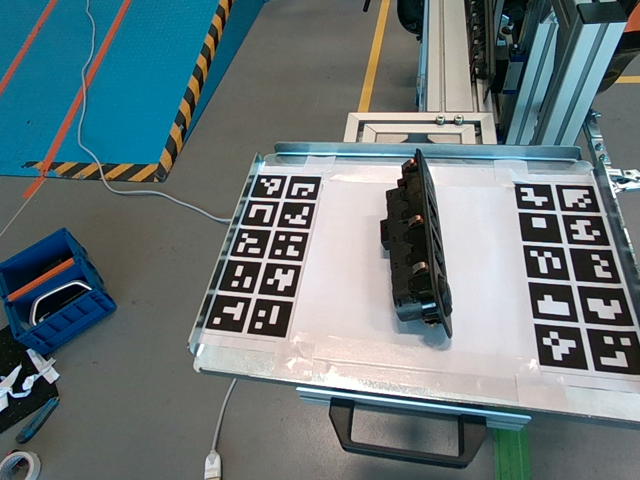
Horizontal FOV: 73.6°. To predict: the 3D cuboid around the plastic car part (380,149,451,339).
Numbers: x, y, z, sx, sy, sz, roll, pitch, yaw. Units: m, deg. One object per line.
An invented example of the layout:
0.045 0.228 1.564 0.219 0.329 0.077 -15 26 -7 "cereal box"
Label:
0.096 0.001 0.436 0.067 0.202 0.066 -12 -38 15 "plastic car part"
